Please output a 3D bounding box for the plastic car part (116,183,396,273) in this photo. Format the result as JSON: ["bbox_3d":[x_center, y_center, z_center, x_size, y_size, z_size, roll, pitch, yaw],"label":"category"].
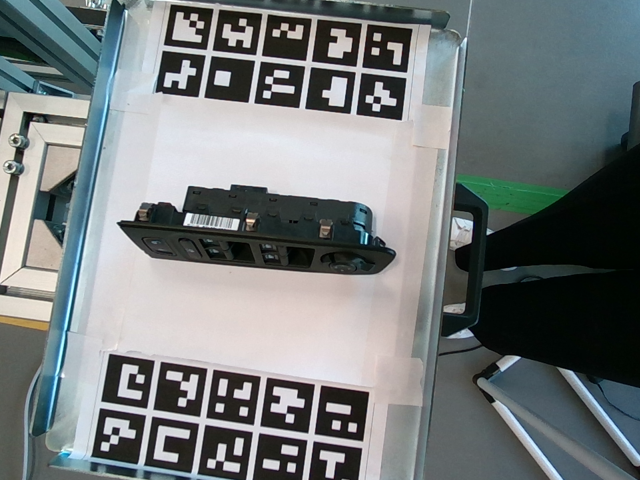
[{"bbox_3d":[-0.043,-0.009,0.339,0.203,0.067,0.066,9,-31,4],"label":"plastic car part"}]
